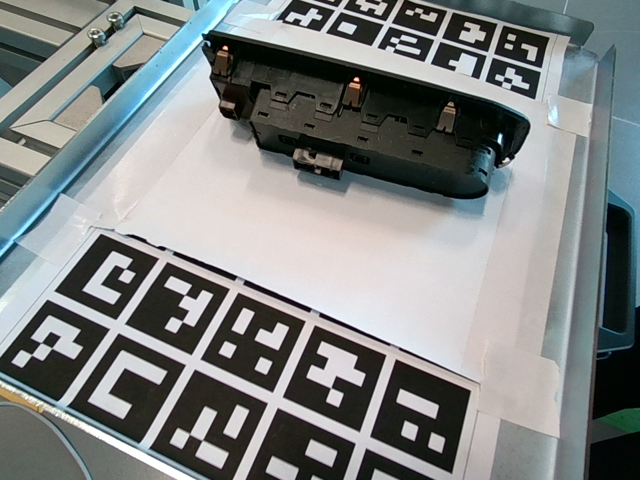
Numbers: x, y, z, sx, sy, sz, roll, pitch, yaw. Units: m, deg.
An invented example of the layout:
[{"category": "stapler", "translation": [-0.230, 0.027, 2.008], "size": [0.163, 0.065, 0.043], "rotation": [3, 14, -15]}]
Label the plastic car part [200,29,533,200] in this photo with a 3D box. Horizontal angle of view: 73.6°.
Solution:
[{"category": "plastic car part", "translation": [0.024, -0.069, 0.260], "size": [0.203, 0.067, 0.066], "rotation": [12, -19, 5]}]
